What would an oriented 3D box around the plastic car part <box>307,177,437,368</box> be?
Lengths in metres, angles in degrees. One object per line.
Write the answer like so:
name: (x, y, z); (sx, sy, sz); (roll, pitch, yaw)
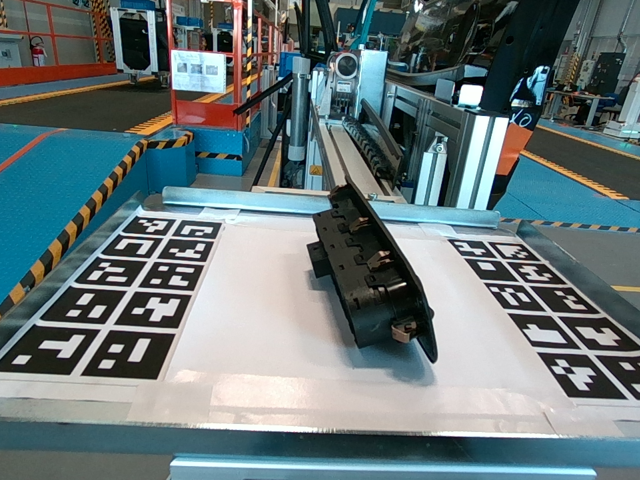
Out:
plastic car part: (0.028, 0.014, 0.317); (0.067, 0.066, 0.203); (-10, 25, -9)
